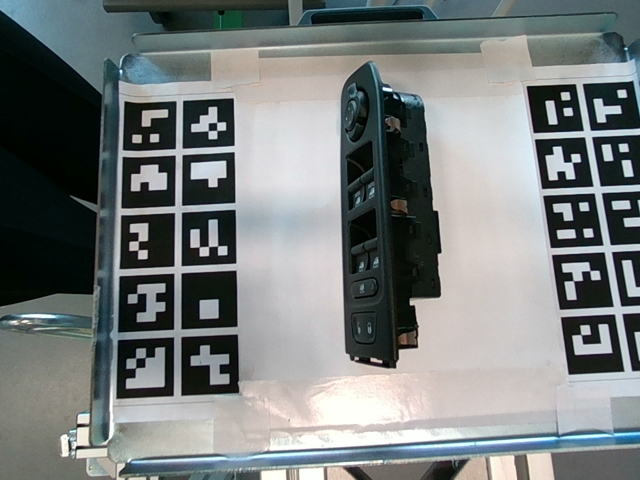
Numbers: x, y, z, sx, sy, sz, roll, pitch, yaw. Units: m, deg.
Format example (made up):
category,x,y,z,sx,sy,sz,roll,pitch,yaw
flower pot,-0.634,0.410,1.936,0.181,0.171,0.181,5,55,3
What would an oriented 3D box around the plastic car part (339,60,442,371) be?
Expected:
category,x,y,z,sx,sy,sz,roll,pitch,yaw
plastic car part,0.046,-0.023,0.285,0.067,0.202,0.066,-4,-9,-12
